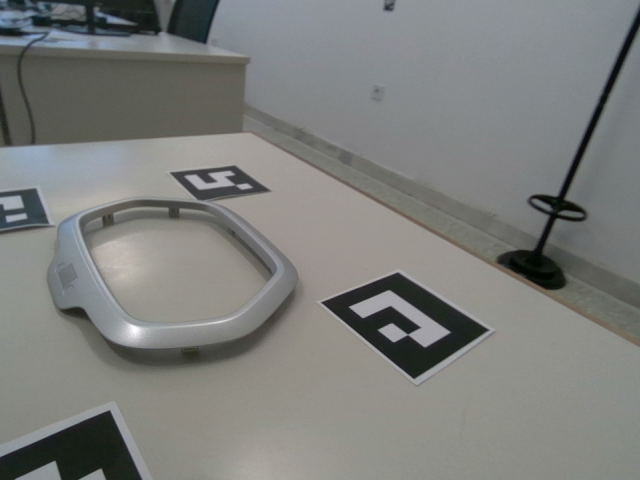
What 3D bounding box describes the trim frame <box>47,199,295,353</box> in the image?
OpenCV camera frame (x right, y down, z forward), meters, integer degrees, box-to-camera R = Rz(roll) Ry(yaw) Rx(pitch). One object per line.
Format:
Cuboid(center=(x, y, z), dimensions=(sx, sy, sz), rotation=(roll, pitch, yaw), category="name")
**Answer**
Cuboid(center=(-0.133, 0.016, 0.378), dimensions=(0.182, 0.027, 0.250), rotation=(-13, 36, -36), category="trim frame")
